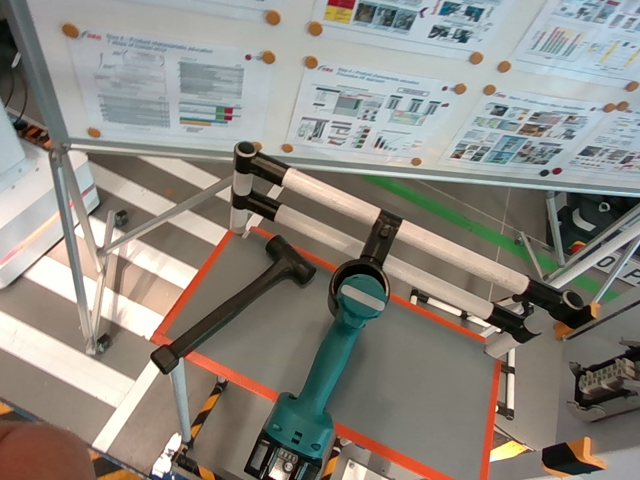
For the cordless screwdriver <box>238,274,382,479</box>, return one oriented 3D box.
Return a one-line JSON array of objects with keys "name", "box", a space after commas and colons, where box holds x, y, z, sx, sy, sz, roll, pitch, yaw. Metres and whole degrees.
[{"name": "cordless screwdriver", "box": [-0.001, 0.159, 0.508, 0.074, 0.248, 0.159, 25, -7, 6]}]
